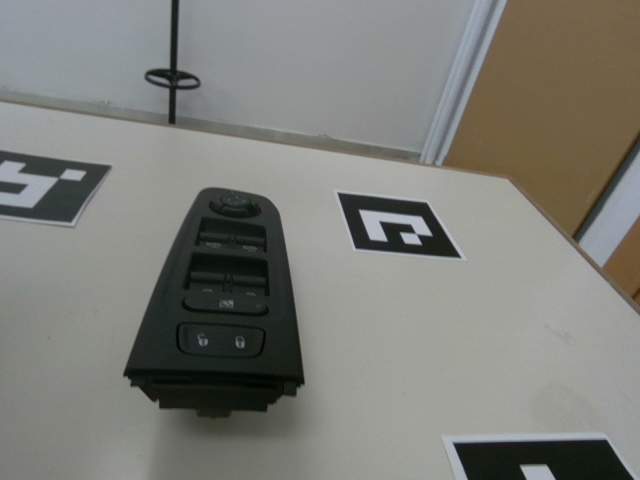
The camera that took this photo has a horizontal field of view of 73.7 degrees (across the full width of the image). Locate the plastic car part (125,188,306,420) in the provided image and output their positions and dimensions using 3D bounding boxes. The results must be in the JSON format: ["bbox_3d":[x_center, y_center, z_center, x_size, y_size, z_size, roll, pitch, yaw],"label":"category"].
[{"bbox_3d":[-0.051,0.025,0.252,0.066,0.067,0.203,0,31,-8],"label":"plastic car part"}]
